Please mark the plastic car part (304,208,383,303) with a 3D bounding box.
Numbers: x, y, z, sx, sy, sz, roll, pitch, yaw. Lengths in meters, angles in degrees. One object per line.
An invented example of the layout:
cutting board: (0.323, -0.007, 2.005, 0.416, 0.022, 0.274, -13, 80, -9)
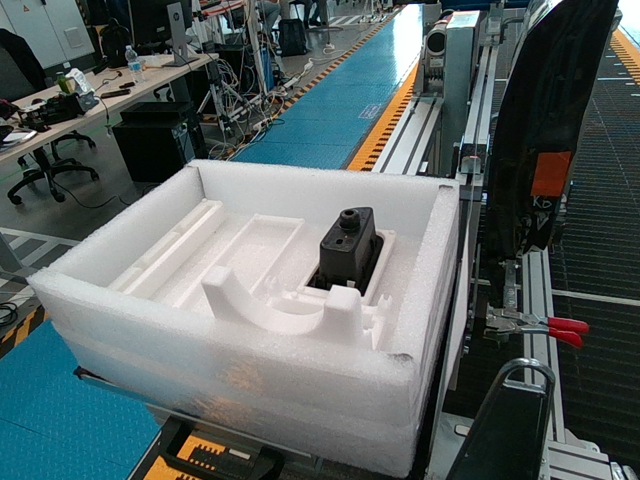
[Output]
plastic car part: (0.031, 0.004, 0.474, 0.066, 0.071, 0.116, 10, 42, 21)
